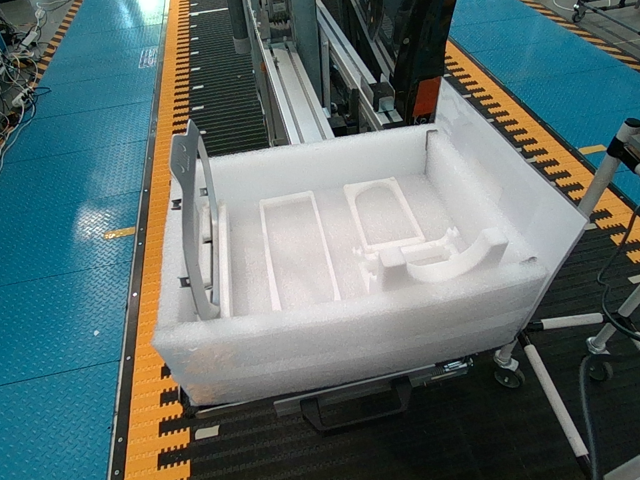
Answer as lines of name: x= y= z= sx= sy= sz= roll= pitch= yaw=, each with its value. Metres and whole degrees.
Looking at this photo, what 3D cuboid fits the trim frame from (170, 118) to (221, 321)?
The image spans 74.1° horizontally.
trim frame: x=-0.134 y=-0.024 z=0.473 sx=0.027 sy=0.248 sz=0.184 roll=-5 pitch=-41 yaw=-6
